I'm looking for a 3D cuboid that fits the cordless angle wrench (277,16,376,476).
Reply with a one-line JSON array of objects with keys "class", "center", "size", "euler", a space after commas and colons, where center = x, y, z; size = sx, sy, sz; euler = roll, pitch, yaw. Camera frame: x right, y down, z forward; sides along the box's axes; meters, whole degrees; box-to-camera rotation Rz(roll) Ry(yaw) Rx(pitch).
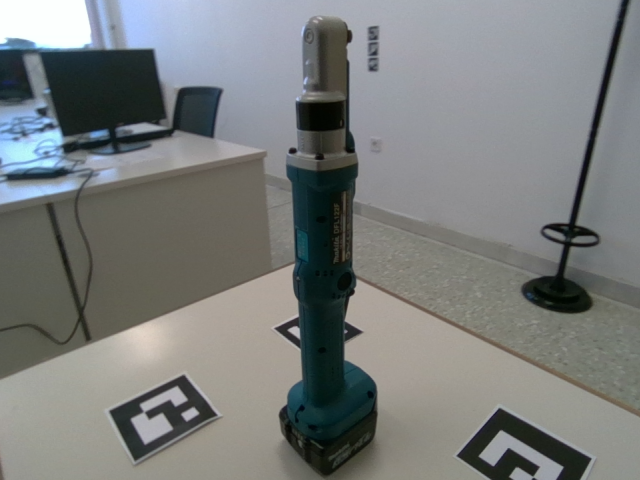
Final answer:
[{"class": "cordless angle wrench", "center": [0.005, 0.029, 0.398], "size": [0.097, 0.423, 0.075], "euler": [-20, 29, -36]}]
